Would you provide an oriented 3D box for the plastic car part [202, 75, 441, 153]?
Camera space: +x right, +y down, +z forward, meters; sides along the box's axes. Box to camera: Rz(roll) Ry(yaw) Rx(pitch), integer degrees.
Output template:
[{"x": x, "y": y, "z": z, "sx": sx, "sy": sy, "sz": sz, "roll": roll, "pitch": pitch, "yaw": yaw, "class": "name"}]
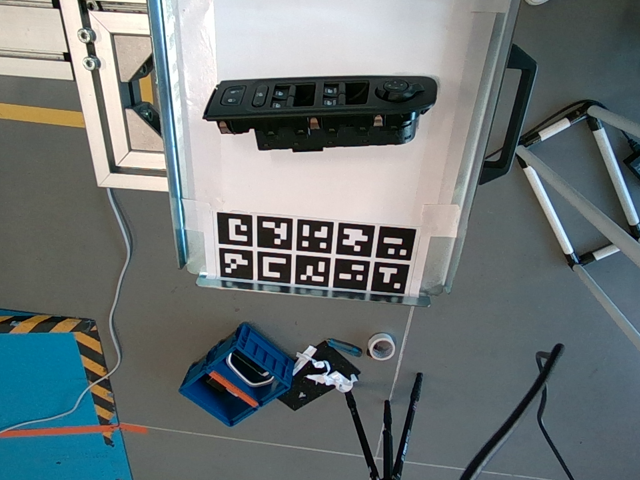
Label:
[{"x": 0.004, "y": -0.109, "z": 0.381, "sx": 0.204, "sy": 0.067, "sz": 0.066, "roll": -2, "pitch": 42, "yaw": 12, "class": "plastic car part"}]
